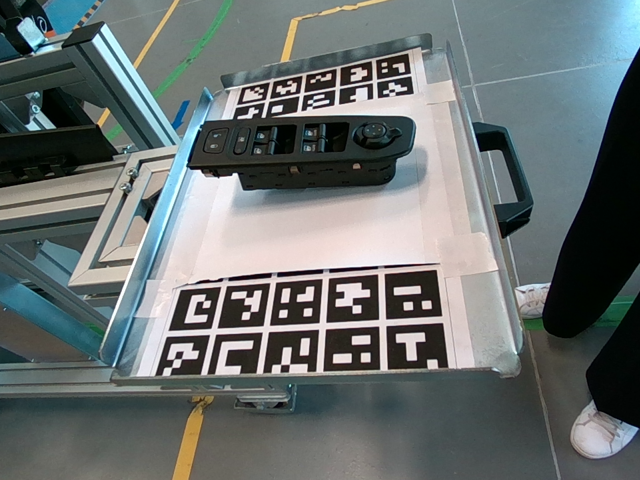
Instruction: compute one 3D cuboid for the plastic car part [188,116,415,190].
[{"bbox_3d":[-0.014,-0.077,0.398,0.203,0.067,0.066,-4,43,10],"label":"plastic car part"}]
